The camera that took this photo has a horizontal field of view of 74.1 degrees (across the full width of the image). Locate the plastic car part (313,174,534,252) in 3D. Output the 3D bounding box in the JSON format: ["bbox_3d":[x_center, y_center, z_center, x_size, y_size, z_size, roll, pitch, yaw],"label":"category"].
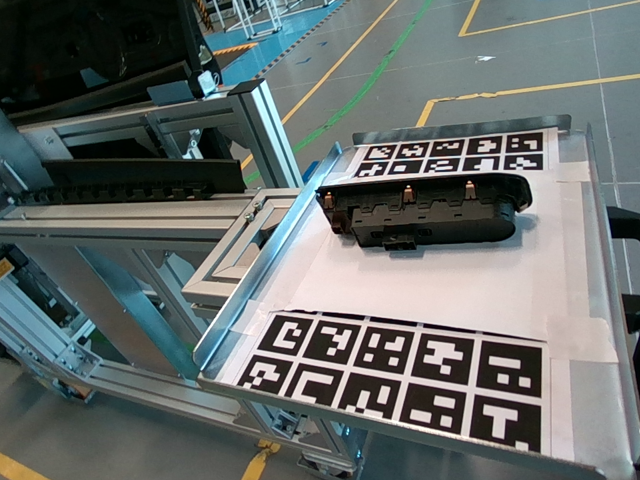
[{"bbox_3d":[0.096,-0.024,0.405,0.204,0.067,0.066,-6,-33,19],"label":"plastic car part"}]
